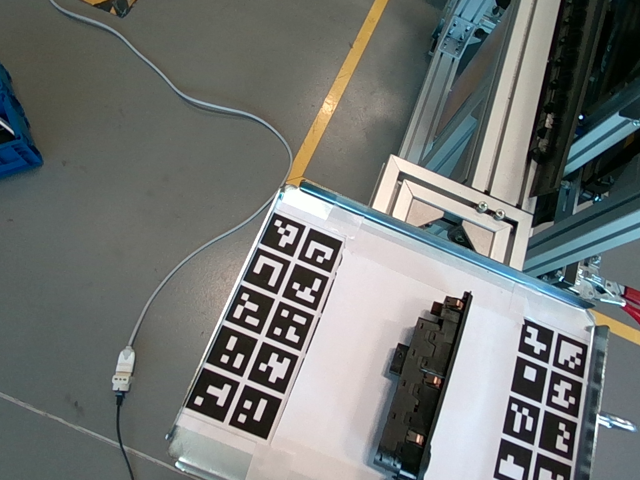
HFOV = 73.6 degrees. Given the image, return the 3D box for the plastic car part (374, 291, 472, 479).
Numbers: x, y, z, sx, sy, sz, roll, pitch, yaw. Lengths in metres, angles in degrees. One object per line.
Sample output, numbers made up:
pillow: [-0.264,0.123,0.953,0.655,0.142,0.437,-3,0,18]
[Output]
plastic car part: [0.101,0.146,0.427,0.067,0.202,0.066,15,-19,9]
